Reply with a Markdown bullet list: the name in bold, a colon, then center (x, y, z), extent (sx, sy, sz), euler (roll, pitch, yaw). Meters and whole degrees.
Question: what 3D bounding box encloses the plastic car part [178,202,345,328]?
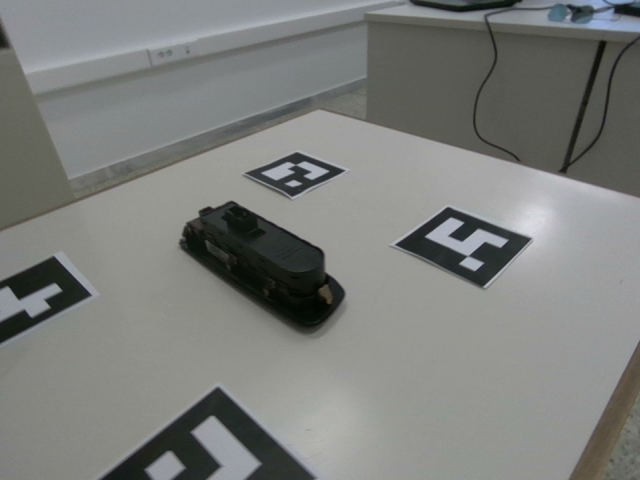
- **plastic car part**: center (-0.058, 0.009, 0.399), extent (0.065, 0.067, 0.205), euler (-23, 41, -39)
